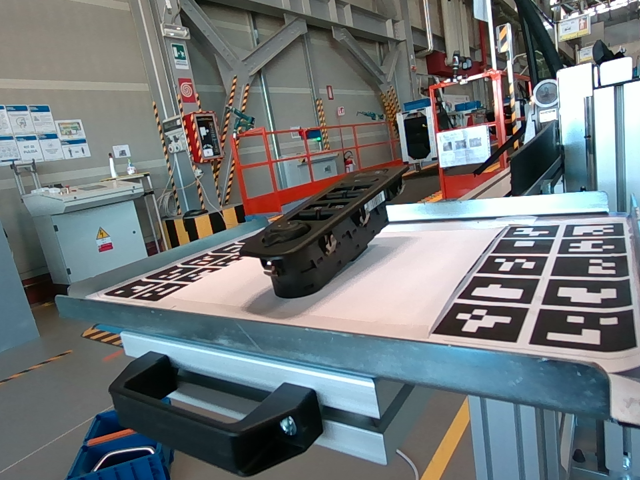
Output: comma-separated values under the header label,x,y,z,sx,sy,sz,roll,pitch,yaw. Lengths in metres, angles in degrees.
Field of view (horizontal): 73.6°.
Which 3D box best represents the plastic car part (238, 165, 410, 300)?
label,x,y,z,sx,sy,sz,roll,pitch,yaw
plastic car part,0.011,-0.010,0.355,0.067,0.067,0.201,7,23,31
